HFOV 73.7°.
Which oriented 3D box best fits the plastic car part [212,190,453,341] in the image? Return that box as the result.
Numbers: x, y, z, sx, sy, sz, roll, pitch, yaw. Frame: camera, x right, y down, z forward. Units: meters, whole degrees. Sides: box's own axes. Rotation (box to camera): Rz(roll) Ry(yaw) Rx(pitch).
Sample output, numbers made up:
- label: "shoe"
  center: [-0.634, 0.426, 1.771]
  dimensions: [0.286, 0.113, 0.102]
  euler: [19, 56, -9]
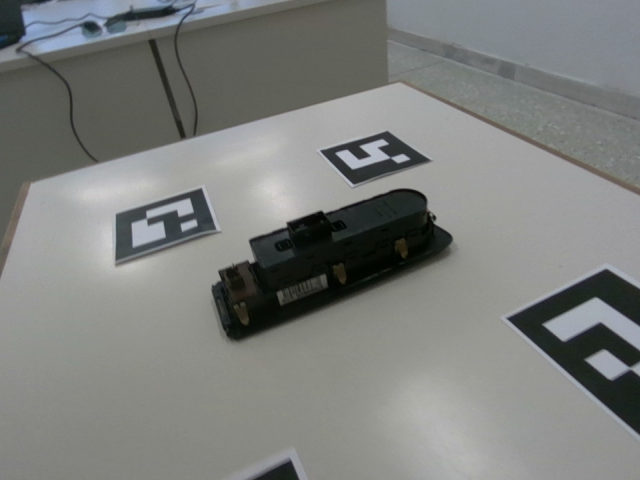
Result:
- label: "plastic car part"
  center: [0.011, 0.006, 0.347]
  dimensions: [0.202, 0.067, 0.067]
  euler: [-17, 29, -15]
